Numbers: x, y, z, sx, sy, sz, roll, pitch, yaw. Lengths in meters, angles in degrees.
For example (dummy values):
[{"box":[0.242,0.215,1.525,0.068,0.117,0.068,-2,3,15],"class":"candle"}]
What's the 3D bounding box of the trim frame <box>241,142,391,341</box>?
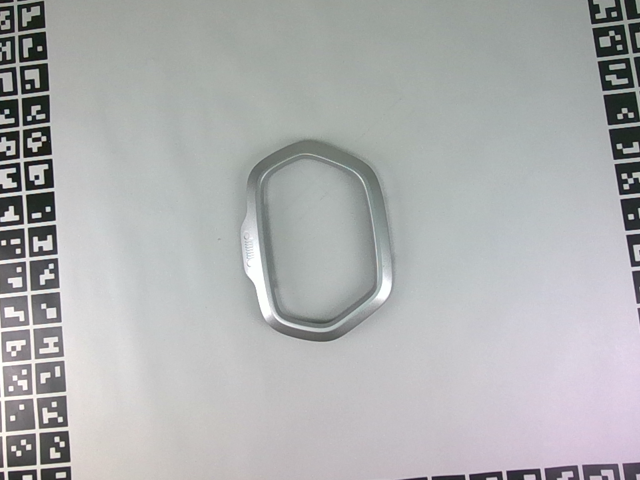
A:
[{"box":[-0.010,-0.001,0.523,0.185,0.248,0.027,-9,-5,8],"class":"trim frame"}]
